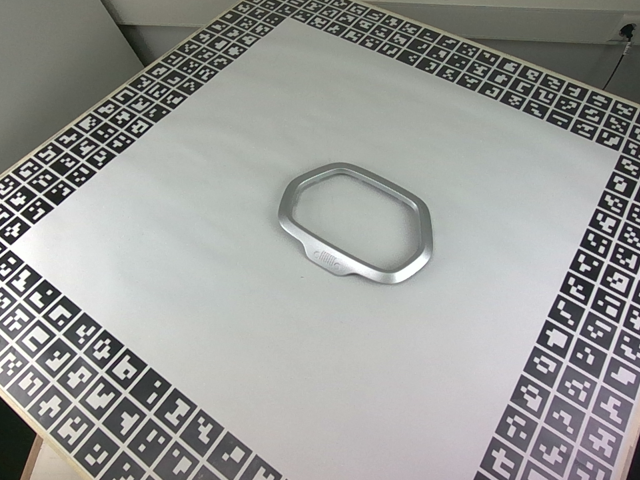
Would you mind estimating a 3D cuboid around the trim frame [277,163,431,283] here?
[{"bbox_3d":[0.053,-0.031,0.653,0.249,0.183,0.027,29,-26,14],"label":"trim frame"}]
